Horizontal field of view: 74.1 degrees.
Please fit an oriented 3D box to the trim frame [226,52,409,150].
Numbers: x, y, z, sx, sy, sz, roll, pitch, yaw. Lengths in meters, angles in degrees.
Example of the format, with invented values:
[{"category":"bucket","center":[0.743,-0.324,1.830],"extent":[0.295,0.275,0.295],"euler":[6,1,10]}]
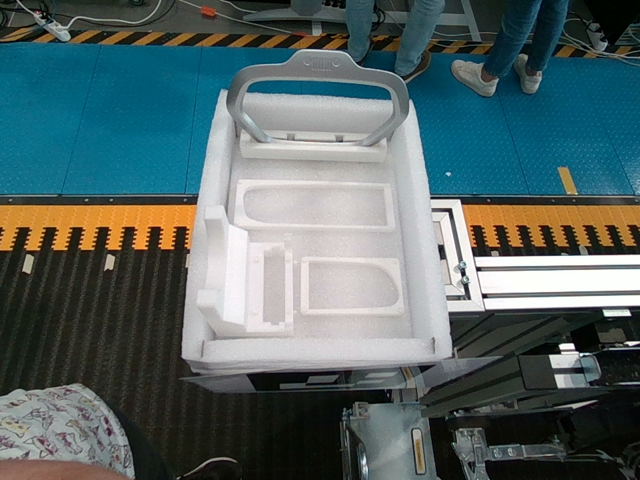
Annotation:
[{"category":"trim frame","center":[-0.003,-0.178,0.578],"extent":[0.248,0.027,0.184],"euler":[2,-21,-1]}]
